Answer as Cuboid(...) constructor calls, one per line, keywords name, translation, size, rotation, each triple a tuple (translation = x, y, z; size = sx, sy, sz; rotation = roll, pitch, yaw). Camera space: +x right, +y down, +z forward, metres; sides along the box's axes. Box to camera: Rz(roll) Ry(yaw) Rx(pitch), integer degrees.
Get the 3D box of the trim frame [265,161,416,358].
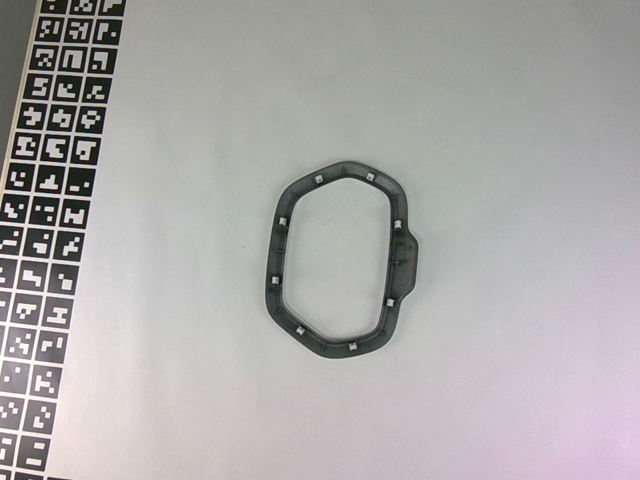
Cuboid(name="trim frame", translation=(0.023, 0.021, 0.527), size=(0.185, 0.248, 0.027), rotation=(7, -7, 10))
